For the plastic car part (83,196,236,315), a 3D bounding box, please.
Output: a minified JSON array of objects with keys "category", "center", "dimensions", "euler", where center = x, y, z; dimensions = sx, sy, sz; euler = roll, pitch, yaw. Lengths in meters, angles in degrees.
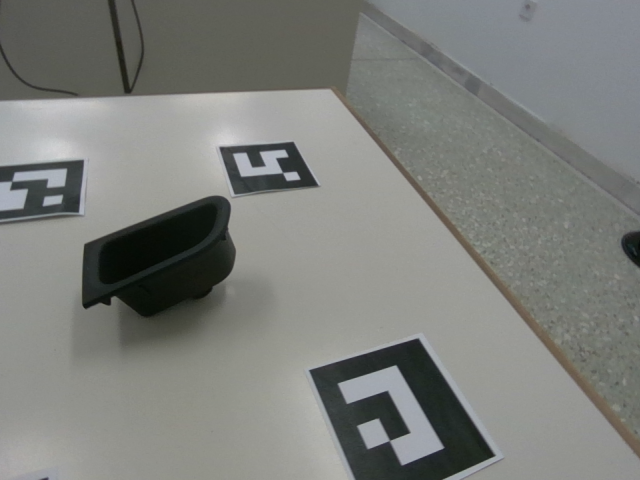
[{"category":"plastic car part","center":[-0.115,0.021,0.340],"dimensions":[0.116,0.066,0.071],"euler":[-21,-40,-7]}]
